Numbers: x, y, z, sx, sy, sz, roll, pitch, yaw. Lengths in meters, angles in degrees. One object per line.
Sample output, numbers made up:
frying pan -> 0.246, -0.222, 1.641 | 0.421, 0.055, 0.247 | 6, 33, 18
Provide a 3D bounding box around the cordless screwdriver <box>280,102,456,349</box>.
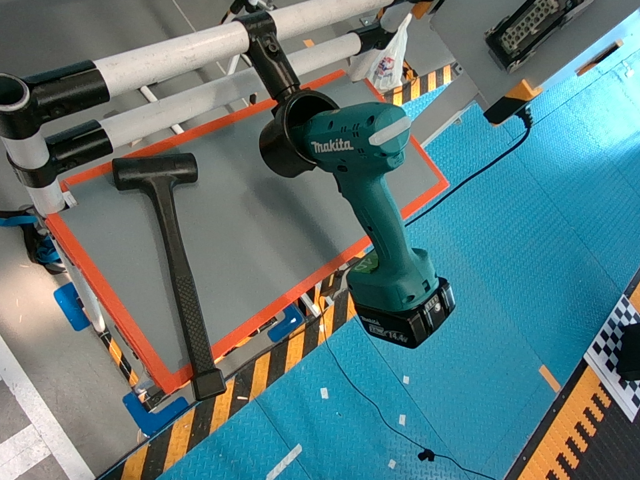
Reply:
cordless screwdriver -> 0.044, -0.013, 0.447 | 0.074, 0.249, 0.159 | -35, 26, -30
